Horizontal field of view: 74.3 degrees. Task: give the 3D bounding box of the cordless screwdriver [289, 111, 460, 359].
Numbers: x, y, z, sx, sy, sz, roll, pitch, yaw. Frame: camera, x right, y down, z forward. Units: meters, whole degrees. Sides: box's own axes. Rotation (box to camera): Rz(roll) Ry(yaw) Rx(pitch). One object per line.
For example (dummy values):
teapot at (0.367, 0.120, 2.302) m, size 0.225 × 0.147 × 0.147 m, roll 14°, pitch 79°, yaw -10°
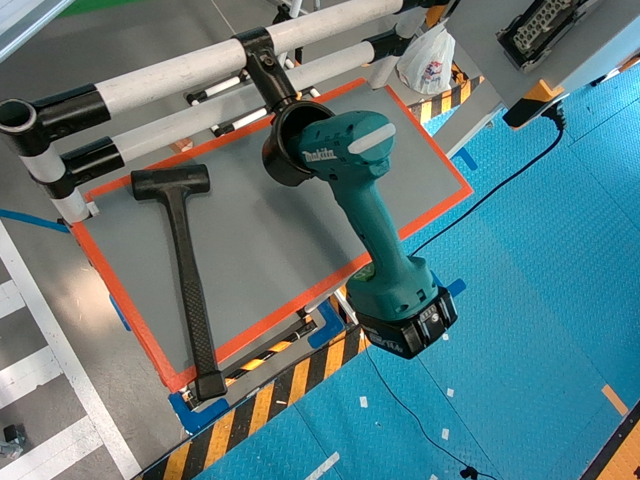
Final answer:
cordless screwdriver at (0.043, -0.006, 0.447) m, size 0.074 × 0.249 × 0.159 m, roll -32°, pitch 21°, yaw -23°
